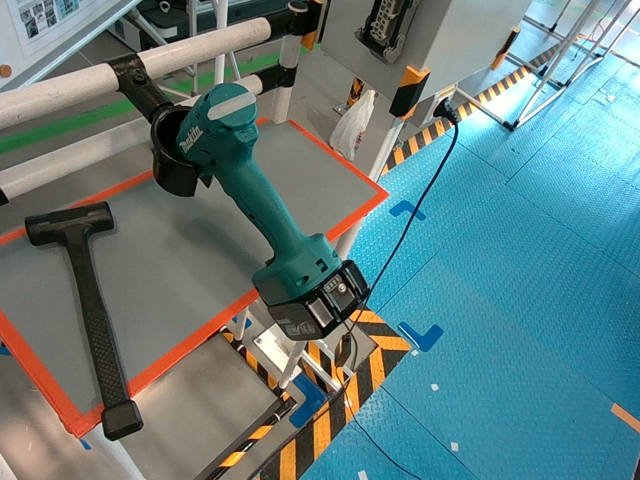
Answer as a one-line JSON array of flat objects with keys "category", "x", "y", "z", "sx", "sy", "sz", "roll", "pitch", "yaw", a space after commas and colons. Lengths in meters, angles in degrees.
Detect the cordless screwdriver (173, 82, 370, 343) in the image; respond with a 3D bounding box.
[{"category": "cordless screwdriver", "x": -0.065, "y": -0.016, "z": 0.434, "sx": 0.074, "sy": 0.249, "sz": 0.159, "roll": -37, "pitch": 12, "yaw": -34}]
